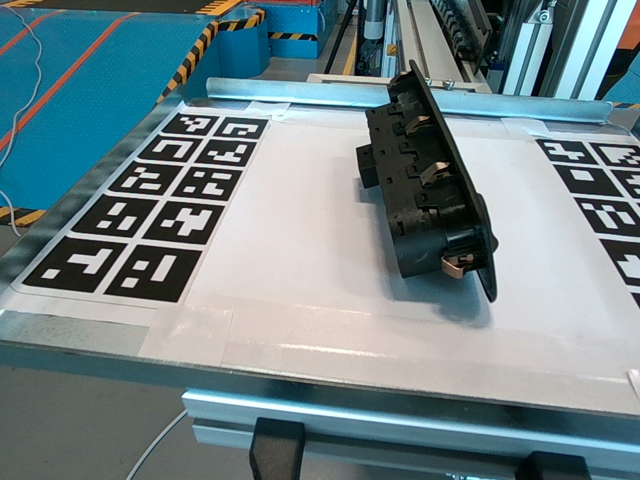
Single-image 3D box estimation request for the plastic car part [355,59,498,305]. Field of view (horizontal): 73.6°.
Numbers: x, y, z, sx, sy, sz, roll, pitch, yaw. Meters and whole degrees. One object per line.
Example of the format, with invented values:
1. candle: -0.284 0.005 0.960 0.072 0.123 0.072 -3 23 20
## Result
1. plastic car part: 0.057 -0.046 0.263 0.067 0.066 0.202 -12 38 6
